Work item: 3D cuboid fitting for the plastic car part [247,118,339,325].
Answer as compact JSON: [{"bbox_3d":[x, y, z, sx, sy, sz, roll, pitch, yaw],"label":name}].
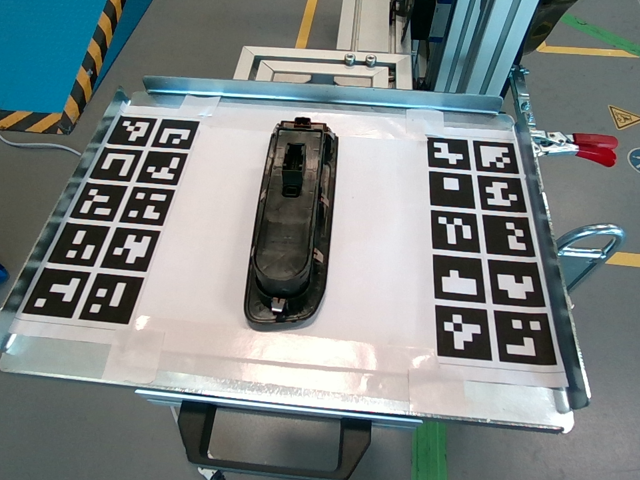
[{"bbox_3d":[-0.018,-0.031,0.347,0.066,0.202,0.067,7,-29,-3],"label":"plastic car part"}]
